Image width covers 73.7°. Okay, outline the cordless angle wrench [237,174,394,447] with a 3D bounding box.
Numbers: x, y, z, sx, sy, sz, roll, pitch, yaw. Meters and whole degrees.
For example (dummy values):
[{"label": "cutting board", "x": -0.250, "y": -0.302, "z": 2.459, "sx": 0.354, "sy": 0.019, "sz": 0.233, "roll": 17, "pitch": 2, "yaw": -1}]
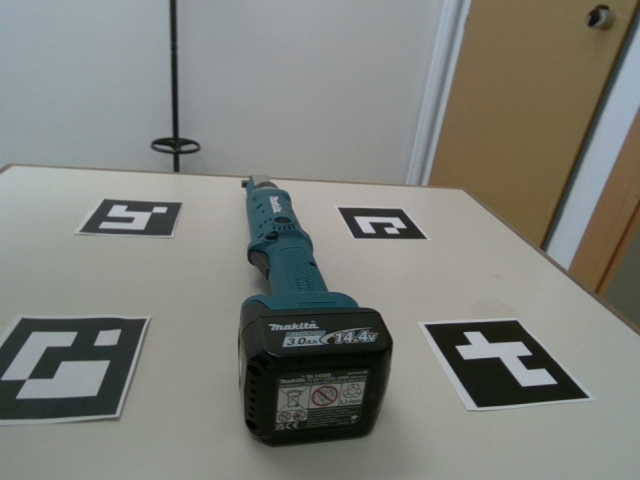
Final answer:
[{"label": "cordless angle wrench", "x": -0.043, "y": 0.005, "z": 0.440, "sx": 0.097, "sy": 0.074, "sz": 0.425, "roll": 1, "pitch": 25, "yaw": -14}]
